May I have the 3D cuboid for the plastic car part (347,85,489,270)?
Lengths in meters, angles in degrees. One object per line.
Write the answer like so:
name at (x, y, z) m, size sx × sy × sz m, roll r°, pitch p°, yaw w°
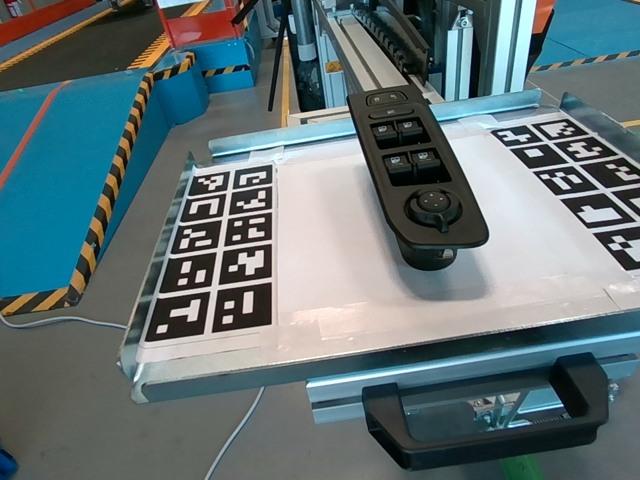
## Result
plastic car part at (0.067, -0.052, 0.341) m, size 0.066 × 0.067 × 0.202 m, roll -4°, pitch 42°, yaw -5°
